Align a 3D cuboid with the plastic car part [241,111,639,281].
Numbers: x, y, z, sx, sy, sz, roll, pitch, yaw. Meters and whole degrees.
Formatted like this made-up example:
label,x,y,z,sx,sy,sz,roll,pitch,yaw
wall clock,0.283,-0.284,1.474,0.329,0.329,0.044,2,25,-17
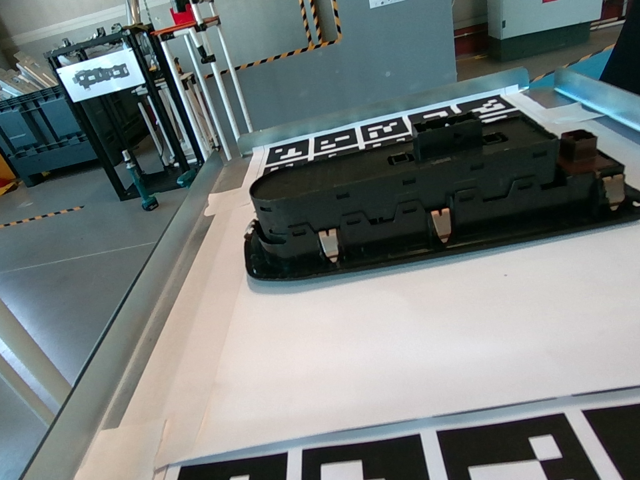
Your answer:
label,x,y,z,sx,sy,sz,roll,pitch,yaw
plastic car part,0.049,-0.024,0.219,0.203,0.067,0.066,-14,37,7
